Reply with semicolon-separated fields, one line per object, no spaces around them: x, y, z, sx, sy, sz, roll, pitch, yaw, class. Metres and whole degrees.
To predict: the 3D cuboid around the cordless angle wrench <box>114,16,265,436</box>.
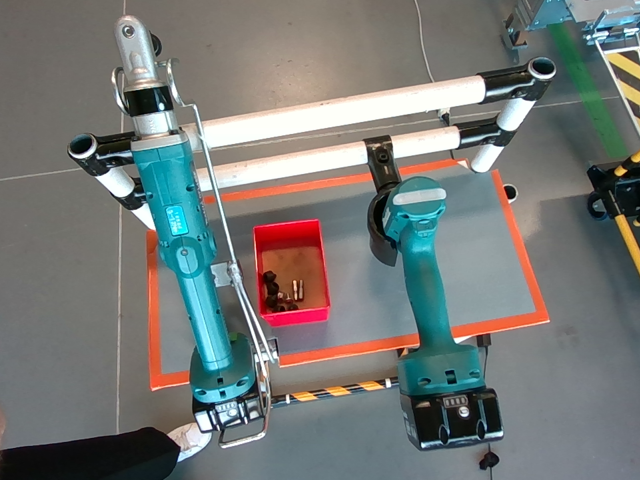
-0.135;0.005;0.434;0.074;0.423;0.098;-12;20;-8;cordless angle wrench

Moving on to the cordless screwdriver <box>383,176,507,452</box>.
0.108;0.074;0.438;0.074;0.248;0.159;-8;-14;0;cordless screwdriver
